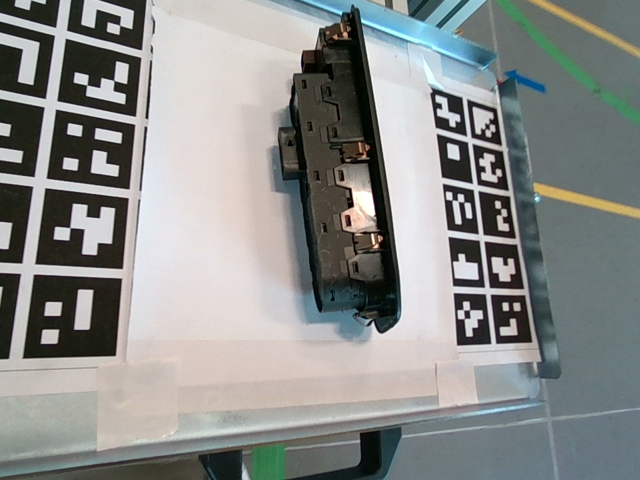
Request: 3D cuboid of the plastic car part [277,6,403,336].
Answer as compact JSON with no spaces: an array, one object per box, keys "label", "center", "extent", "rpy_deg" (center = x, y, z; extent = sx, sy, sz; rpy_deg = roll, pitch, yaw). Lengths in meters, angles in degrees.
[{"label":"plastic car part","center":[0.011,-0.040,0.268],"extent":[0.067,0.202,0.066],"rpy_deg":[-8,-12,-18]}]
